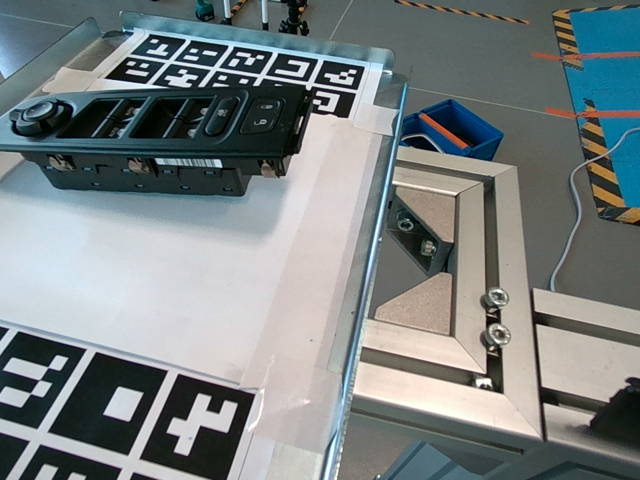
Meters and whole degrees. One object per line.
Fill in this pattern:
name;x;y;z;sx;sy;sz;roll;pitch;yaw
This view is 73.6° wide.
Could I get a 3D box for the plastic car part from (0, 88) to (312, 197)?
plastic car part;-0.107;-0.060;0.272;0.203;0.066;0.067;6;-33;8
